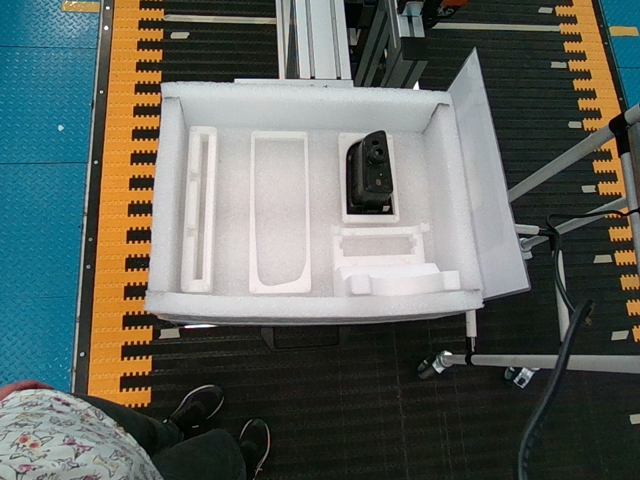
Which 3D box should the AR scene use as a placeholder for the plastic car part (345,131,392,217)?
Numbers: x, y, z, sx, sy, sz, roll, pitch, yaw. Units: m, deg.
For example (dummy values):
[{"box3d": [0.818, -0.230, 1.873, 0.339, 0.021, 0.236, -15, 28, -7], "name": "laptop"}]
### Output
[{"box3d": [0.069, -0.094, 0.568, 0.066, 0.116, 0.071, 1, -12, -8], "name": "plastic car part"}]
